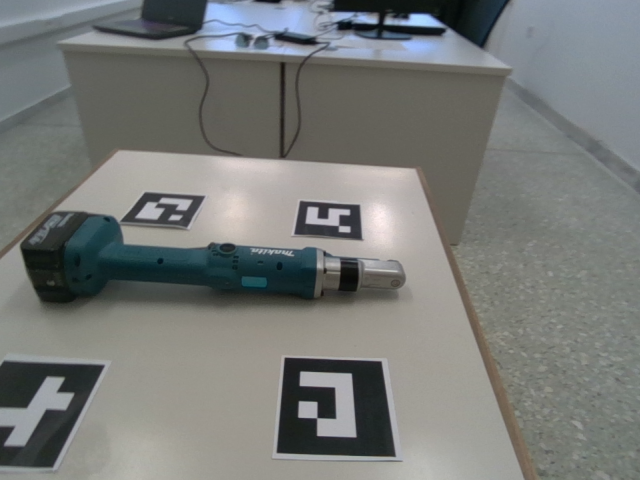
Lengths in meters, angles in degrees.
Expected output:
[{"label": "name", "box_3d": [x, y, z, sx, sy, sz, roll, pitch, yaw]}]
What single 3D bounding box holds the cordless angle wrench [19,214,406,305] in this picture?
[{"label": "cordless angle wrench", "box_3d": [-0.110, 0.031, 0.501, 0.422, 0.074, 0.098, 3, 31, -2]}]
